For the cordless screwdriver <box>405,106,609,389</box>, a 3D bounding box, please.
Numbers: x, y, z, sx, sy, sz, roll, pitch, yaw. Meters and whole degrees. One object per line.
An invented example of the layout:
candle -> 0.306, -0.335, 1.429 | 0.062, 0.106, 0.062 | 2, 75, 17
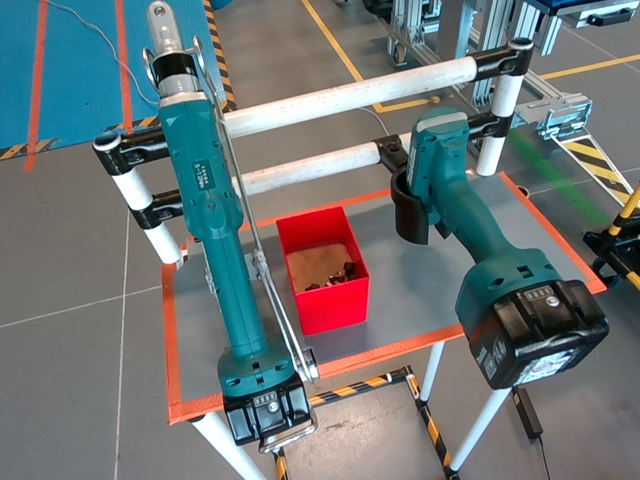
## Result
cordless screwdriver -> 0.143, 0.011, 0.404 | 0.074, 0.248, 0.159 | -14, -33, -3

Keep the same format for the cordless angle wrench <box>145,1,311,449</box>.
cordless angle wrench -> -0.103, -0.024, 0.411 | 0.074, 0.423, 0.098 | -15, 0, -12
